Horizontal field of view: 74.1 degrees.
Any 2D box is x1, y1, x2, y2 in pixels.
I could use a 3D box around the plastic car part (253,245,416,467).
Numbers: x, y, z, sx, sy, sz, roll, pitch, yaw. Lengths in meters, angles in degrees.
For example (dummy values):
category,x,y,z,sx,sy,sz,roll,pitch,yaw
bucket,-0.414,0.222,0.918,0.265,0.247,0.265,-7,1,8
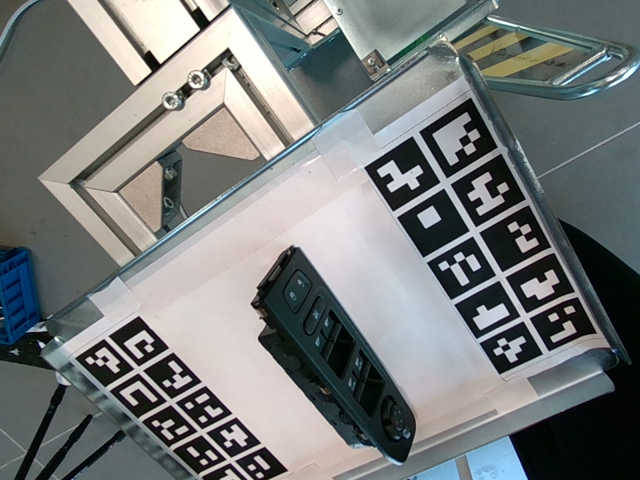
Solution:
category,x,y,z,sx,sy,sz,roll,pitch,yaw
plastic car part,0.010,0.107,0.339,0.067,0.202,0.066,-31,18,25
